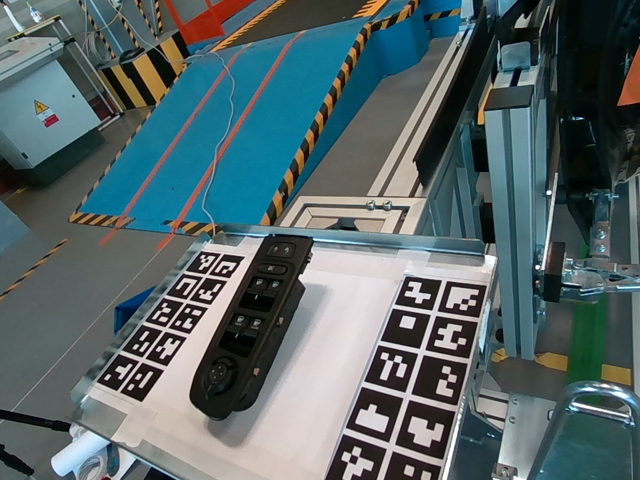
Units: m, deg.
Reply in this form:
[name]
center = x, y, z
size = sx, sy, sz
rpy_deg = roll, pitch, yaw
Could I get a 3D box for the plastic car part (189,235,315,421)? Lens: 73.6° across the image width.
[plastic car part]
center = -0.064, 0.087, 0.443
size = 0.067, 0.202, 0.067
rpy_deg = 9, -37, 25
